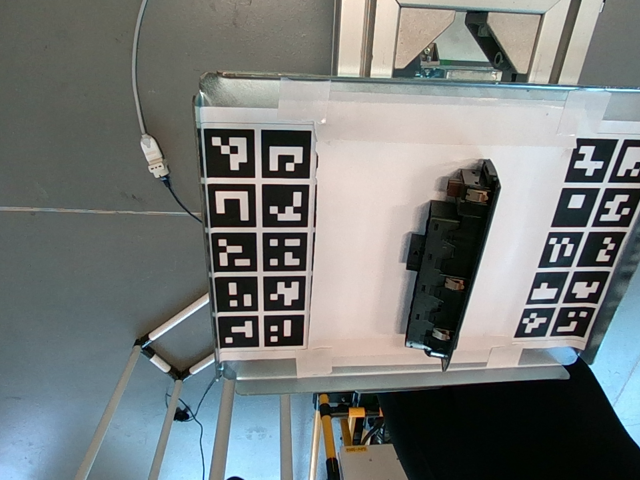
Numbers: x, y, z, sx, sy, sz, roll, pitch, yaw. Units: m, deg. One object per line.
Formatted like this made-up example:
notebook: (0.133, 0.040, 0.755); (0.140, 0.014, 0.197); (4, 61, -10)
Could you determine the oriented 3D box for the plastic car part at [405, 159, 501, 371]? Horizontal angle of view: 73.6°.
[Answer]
plastic car part: (0.111, 0.032, 0.386); (0.067, 0.203, 0.066); (3, 25, 5)
